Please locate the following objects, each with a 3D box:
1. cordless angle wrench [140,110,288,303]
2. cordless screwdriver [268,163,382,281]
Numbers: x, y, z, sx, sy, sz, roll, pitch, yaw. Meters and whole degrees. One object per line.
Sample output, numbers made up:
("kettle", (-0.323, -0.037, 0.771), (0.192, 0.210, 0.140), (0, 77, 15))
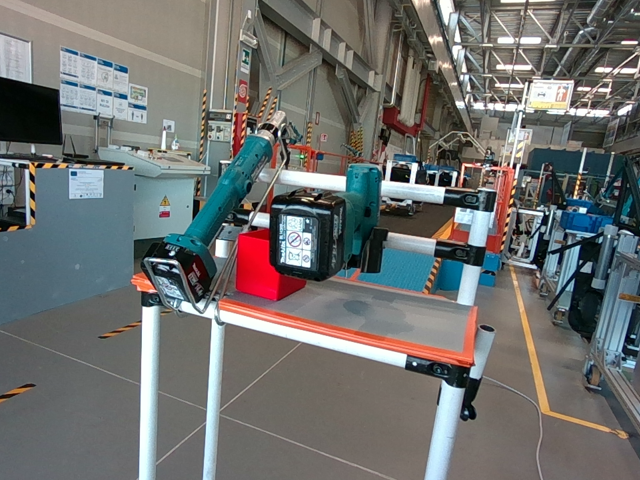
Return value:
("cordless angle wrench", (-0.147, -0.092, 0.729), (0.074, 0.421, 0.098), (14, -35, 16))
("cordless screwdriver", (0.024, -0.009, 0.559), (0.074, 0.159, 0.248), (8, 19, 22))
